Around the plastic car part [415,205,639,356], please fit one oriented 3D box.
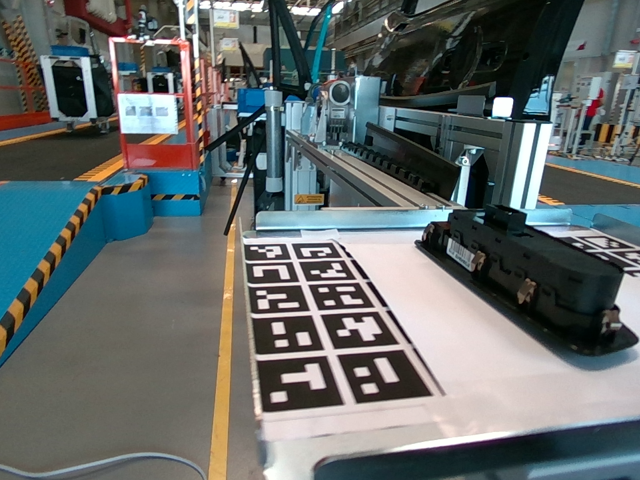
[{"bbox_3d":[0.149,0.014,0.327,0.066,0.067,0.203,4,21,-15],"label":"plastic car part"}]
